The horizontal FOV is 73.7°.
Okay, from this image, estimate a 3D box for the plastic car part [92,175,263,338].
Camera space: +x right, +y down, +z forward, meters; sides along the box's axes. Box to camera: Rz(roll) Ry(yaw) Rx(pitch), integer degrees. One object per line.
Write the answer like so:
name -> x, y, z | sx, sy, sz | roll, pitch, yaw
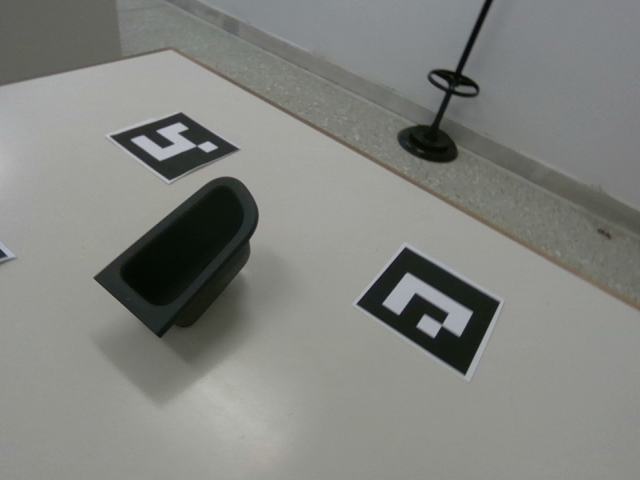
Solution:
plastic car part -> -0.083, 0.017, 0.306 | 0.066, 0.116, 0.071 | 33, -29, 20
